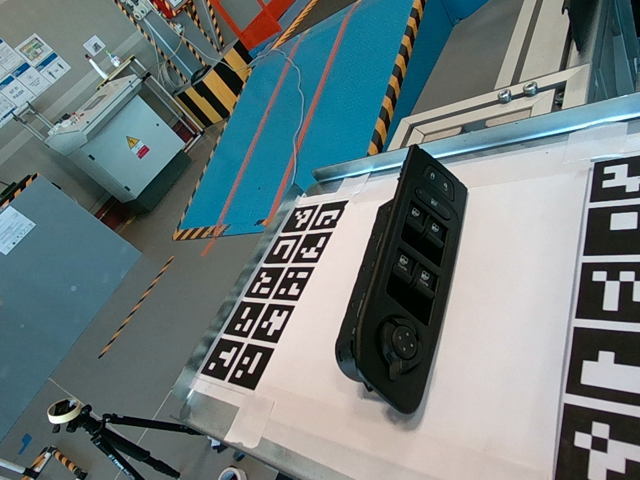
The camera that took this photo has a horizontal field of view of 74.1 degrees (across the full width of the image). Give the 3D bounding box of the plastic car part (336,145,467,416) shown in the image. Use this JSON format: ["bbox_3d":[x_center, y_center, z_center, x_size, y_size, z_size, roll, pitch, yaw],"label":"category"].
[{"bbox_3d":[0.056,0.021,0.311,0.066,0.202,0.067,39,-42,-24],"label":"plastic car part"}]
